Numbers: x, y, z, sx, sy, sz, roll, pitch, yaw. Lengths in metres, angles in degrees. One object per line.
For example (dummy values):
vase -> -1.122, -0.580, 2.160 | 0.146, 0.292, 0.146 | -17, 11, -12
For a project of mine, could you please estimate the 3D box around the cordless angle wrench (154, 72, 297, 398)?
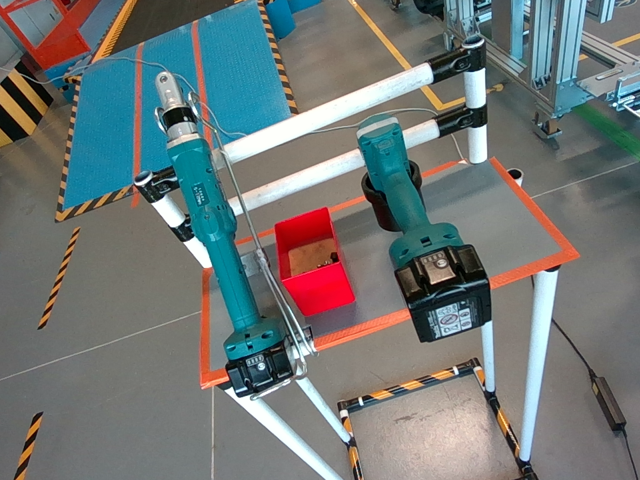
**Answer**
cordless angle wrench -> -0.135, -0.020, 0.541 | 0.074, 0.422, 0.098 | -20, -4, -2

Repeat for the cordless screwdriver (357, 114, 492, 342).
cordless screwdriver -> 0.105, -0.009, 0.477 | 0.074, 0.248, 0.159 | -19, -38, 6
